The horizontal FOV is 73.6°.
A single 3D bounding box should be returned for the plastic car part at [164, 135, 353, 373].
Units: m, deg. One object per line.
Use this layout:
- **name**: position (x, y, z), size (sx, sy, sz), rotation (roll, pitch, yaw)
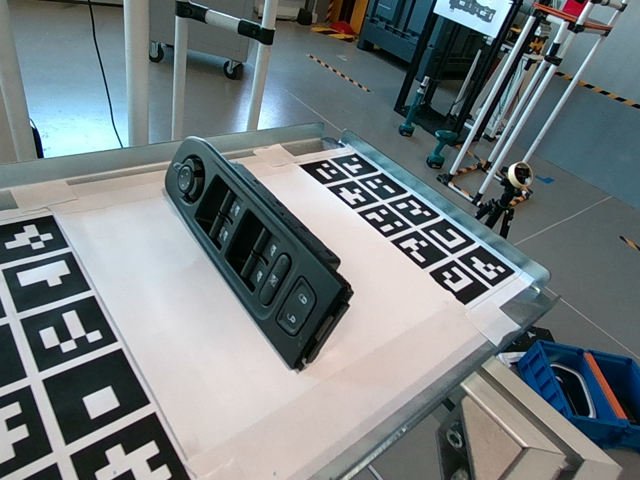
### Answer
- **plastic car part**: position (-0.046, -0.009, 0.309), size (0.066, 0.066, 0.203), rotation (-15, 49, -47)
